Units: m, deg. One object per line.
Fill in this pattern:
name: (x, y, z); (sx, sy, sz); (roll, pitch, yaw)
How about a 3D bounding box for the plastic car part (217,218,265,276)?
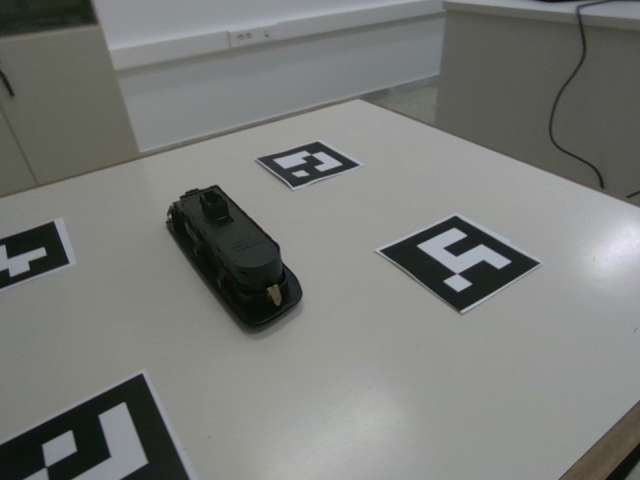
plastic car part: (-0.125, -0.020, 0.547); (0.065, 0.067, 0.205); (-16, 37, -37)
